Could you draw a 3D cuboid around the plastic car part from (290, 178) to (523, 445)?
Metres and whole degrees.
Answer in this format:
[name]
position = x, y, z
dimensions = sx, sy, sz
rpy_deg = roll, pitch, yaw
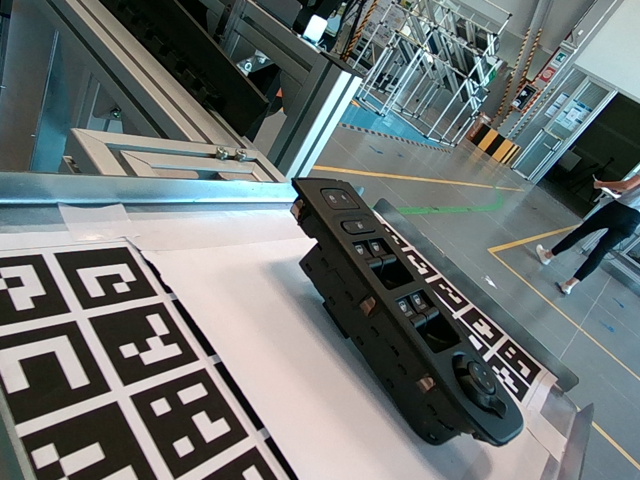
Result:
[plastic car part]
position = 0.042, 0.047, 0.281
dimensions = 0.067, 0.203, 0.066
rpy_deg = -49, -23, 22
